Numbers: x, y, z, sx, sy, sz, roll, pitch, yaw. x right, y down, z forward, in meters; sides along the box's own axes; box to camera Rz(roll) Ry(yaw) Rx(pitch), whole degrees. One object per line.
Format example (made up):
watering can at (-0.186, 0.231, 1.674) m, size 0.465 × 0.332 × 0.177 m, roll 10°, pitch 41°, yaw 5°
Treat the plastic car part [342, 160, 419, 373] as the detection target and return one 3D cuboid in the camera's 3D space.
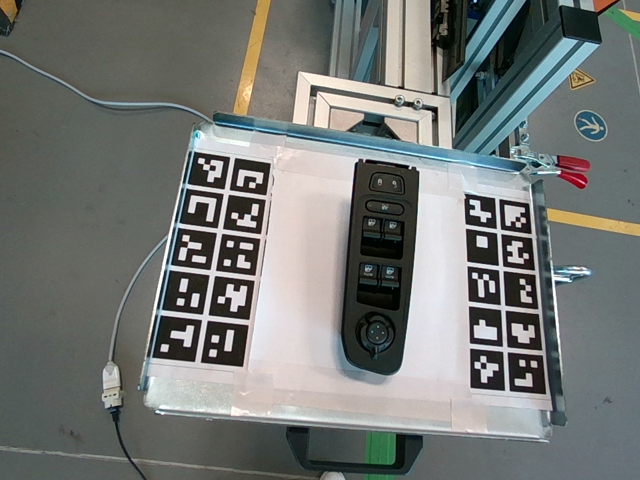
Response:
plastic car part at (0.052, 0.026, 0.424) m, size 0.066 × 0.202 × 0.067 m, roll 9°, pitch -16°, yaw -15°
